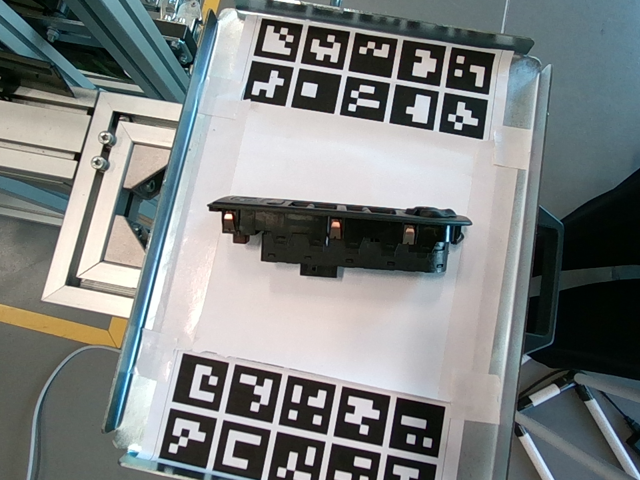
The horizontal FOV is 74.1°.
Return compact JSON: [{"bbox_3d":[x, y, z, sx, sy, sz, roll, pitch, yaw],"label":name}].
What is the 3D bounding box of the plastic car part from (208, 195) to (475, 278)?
[{"bbox_3d":[0.019,-0.003,0.334,0.203,0.067,0.066,1,1,2],"label":"plastic car part"}]
